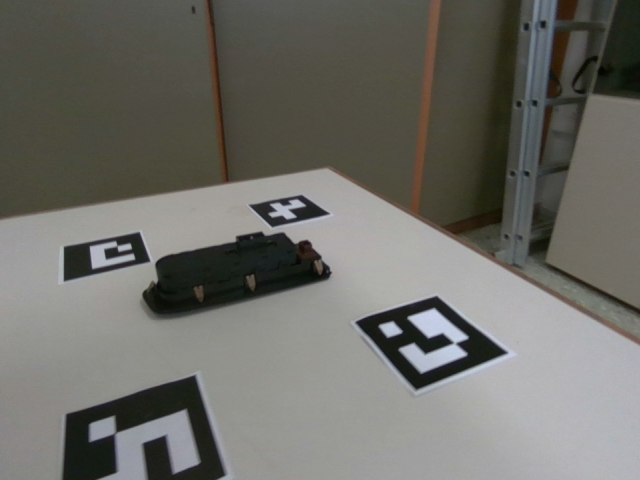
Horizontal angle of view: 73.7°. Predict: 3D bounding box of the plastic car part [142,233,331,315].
[{"bbox_3d":[-0.090,0.032,0.467,0.201,0.067,0.067,-16,35,-22],"label":"plastic car part"}]
